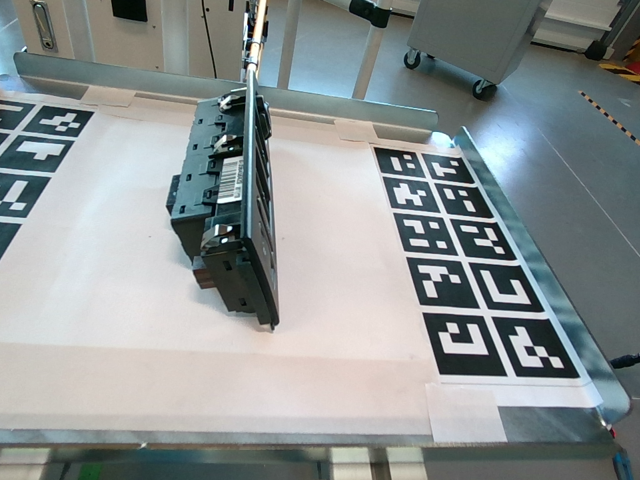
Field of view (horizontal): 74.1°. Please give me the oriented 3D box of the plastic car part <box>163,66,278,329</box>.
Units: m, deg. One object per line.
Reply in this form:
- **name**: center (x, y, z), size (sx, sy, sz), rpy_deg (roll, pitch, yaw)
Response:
- **plastic car part**: center (-0.058, -0.041, 0.270), size (0.068, 0.203, 0.066), rpy_deg (-12, -45, 9)
